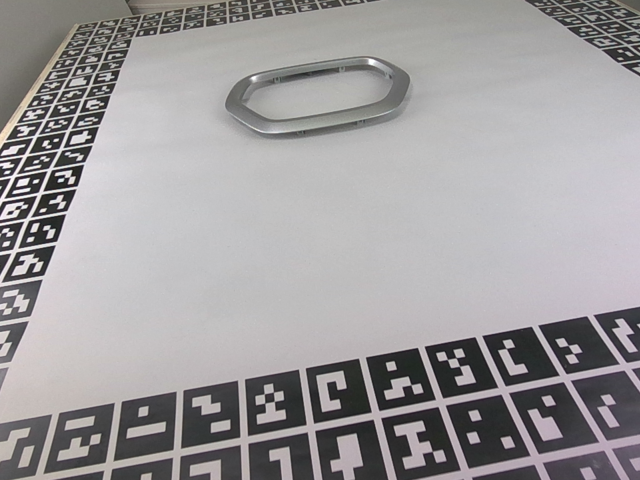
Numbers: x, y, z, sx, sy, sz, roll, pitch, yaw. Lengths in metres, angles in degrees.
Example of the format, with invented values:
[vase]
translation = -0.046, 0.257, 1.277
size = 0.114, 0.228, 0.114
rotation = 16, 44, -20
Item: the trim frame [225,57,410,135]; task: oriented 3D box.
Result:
[trim frame]
translation = -0.003, -0.196, 0.563
size = 0.248, 0.184, 0.027
rotation = -13, -43, -4
